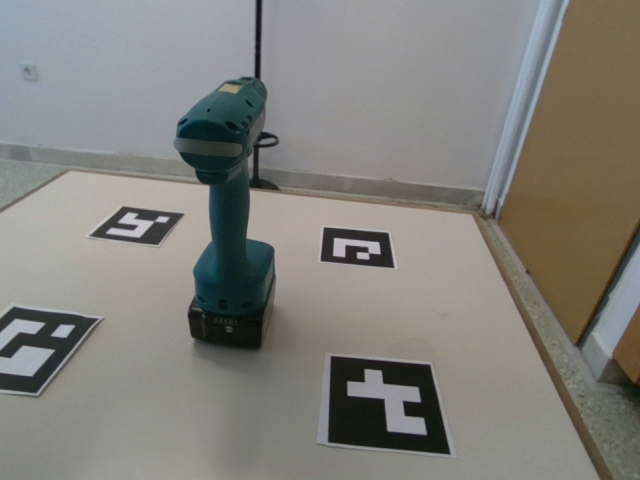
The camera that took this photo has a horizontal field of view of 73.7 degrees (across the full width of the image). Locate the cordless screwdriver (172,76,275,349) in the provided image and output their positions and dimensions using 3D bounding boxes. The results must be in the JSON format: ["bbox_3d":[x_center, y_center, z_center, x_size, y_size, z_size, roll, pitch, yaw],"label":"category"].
[{"bbox_3d":[-0.079,-0.025,0.414,0.074,0.249,0.159,7,35,2],"label":"cordless screwdriver"}]
